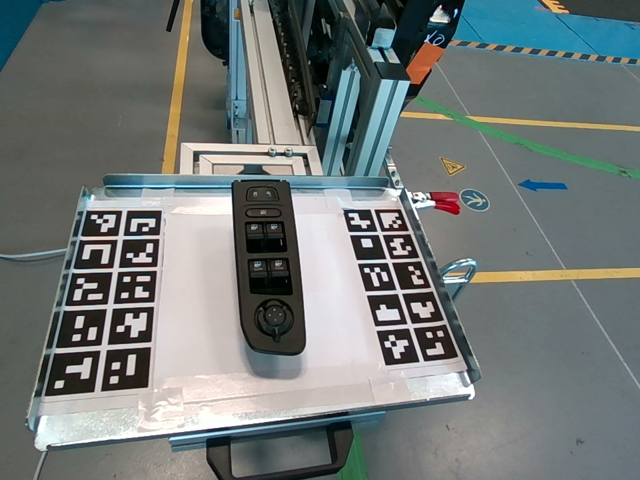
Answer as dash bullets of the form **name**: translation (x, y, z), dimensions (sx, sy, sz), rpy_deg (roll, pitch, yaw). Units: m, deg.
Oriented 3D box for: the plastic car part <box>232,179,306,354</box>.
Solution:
- **plastic car part**: translation (-0.059, 0.029, 0.453), dimensions (0.066, 0.202, 0.067), rpy_deg (3, -36, -20)
